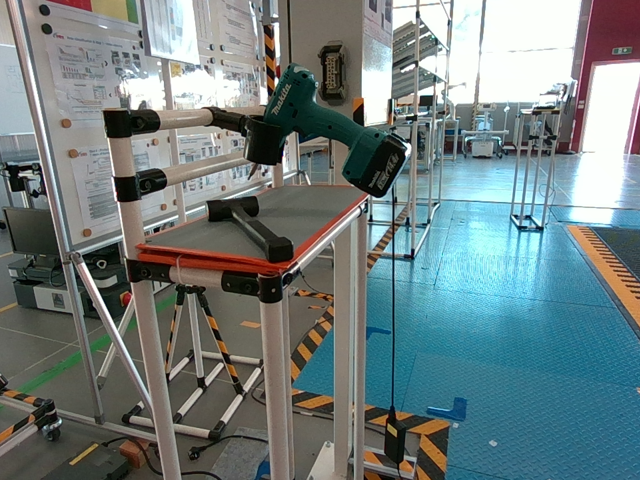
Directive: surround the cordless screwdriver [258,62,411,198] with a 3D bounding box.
[{"bbox_3d":[0.014,-0.157,0.701,0.249,0.159,0.074,35,27,4],"label":"cordless screwdriver"}]
